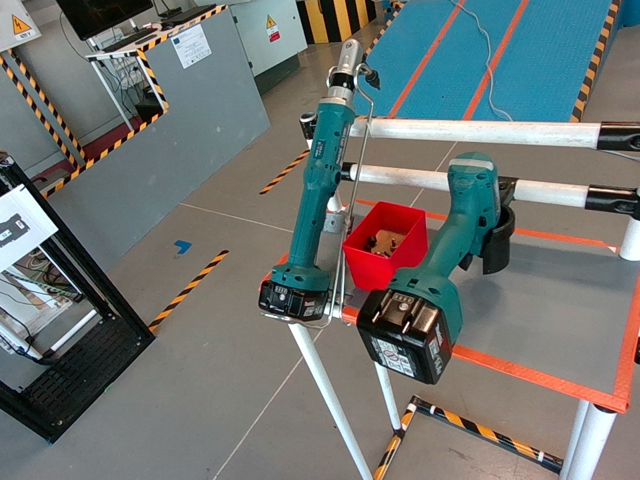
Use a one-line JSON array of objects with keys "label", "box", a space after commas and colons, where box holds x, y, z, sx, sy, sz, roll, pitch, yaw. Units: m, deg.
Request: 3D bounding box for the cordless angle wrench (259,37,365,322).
[{"label": "cordless angle wrench", "box": [0.005, -0.093, 0.631, 0.074, 0.423, 0.098, 13, 0, 28]}]

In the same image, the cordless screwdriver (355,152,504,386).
[{"label": "cordless screwdriver", "box": [0.144, 0.039, 0.474, 0.074, 0.248, 0.159, 14, -33, 38]}]
